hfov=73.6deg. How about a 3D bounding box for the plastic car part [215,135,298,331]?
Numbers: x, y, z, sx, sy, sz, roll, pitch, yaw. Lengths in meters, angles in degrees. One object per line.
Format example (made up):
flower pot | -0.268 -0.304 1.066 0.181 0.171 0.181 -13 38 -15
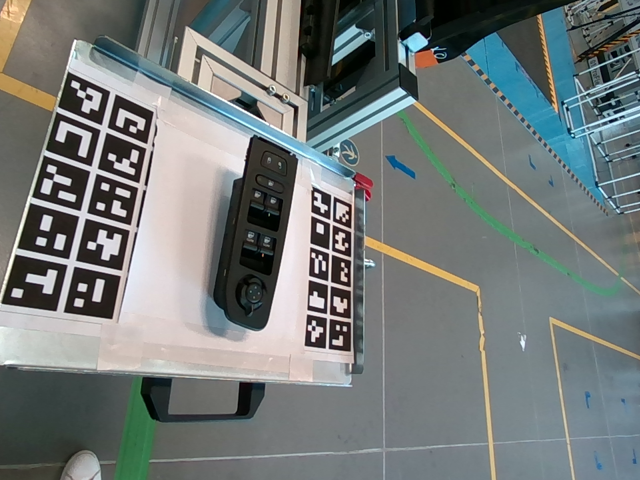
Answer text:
plastic car part | -0.077 -0.006 0.466 0.067 0.202 0.066 -9 -21 38
